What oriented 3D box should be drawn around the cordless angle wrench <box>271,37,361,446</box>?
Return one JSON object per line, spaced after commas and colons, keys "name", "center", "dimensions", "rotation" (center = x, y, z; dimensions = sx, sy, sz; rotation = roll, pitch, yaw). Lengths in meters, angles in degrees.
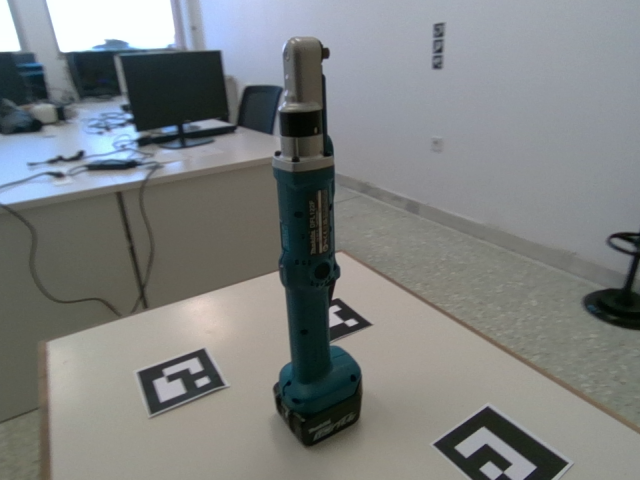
{"name": "cordless angle wrench", "center": [-0.011, 0.023, 0.444], "dimensions": [0.097, 0.422, 0.075], "rotation": [-15, 26, -28]}
